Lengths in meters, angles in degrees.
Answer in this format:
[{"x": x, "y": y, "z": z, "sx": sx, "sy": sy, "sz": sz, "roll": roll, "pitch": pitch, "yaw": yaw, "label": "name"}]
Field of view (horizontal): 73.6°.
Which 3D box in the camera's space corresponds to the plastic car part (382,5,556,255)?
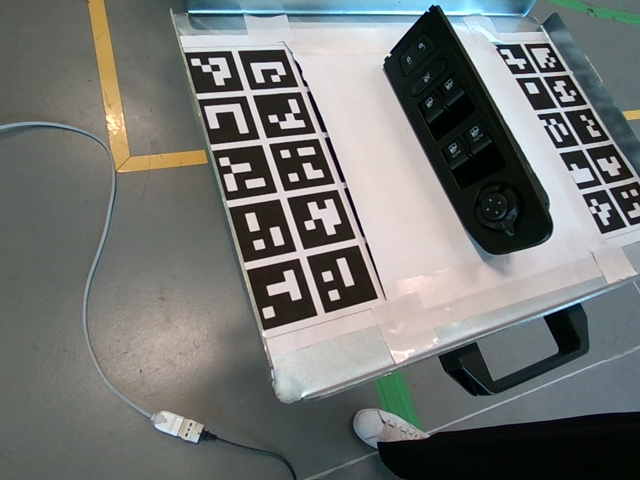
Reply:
[{"x": 0.122, "y": -0.082, "z": 0.343, "sx": 0.067, "sy": 0.203, "sz": 0.067, "roll": 3, "pitch": -28, "yaw": -46, "label": "plastic car part"}]
